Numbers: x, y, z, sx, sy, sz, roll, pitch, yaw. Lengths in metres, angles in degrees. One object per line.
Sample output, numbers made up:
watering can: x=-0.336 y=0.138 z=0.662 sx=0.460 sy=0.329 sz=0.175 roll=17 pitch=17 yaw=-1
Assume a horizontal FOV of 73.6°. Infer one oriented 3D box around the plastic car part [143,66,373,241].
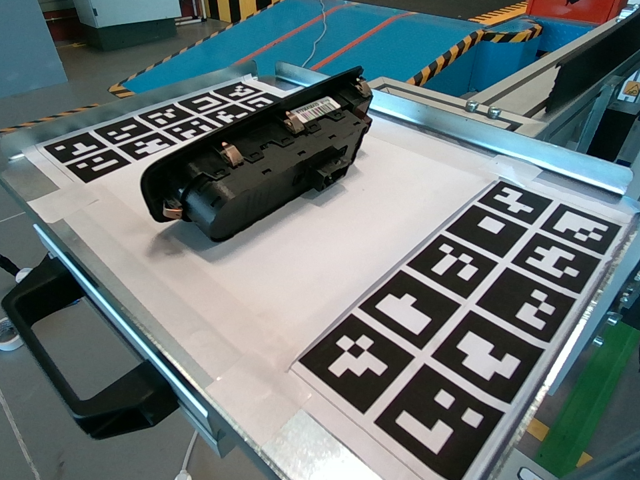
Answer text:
plastic car part: x=-0.025 y=-0.057 z=0.304 sx=0.202 sy=0.067 sz=0.067 roll=-32 pitch=-14 yaw=-35
